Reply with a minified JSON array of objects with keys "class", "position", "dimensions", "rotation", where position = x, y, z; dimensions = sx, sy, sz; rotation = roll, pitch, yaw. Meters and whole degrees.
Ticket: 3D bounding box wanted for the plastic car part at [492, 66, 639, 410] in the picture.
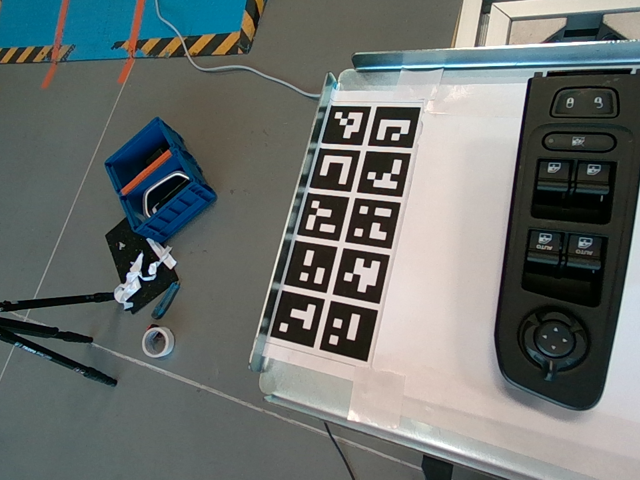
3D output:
[{"class":"plastic car part","position":[0.151,-0.002,0.270],"dimensions":[0.066,0.202,0.067],"rotation":[9,-9,17]}]
